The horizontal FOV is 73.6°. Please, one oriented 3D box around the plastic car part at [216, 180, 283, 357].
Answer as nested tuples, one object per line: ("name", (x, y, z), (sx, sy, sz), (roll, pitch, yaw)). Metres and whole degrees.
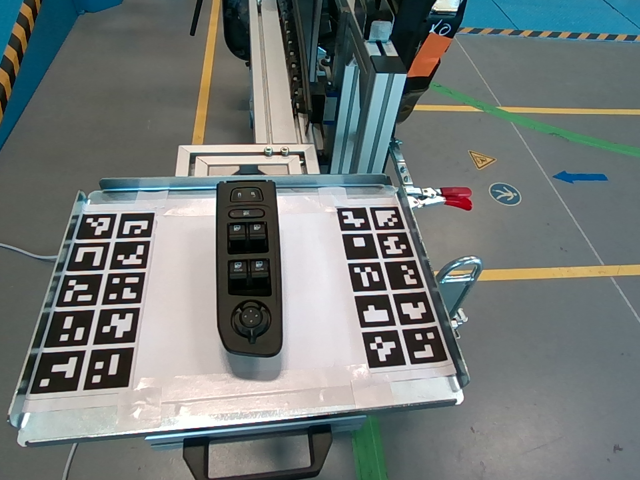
("plastic car part", (-0.077, 0.030, 0.452), (0.066, 0.202, 0.067), (1, -36, -15))
